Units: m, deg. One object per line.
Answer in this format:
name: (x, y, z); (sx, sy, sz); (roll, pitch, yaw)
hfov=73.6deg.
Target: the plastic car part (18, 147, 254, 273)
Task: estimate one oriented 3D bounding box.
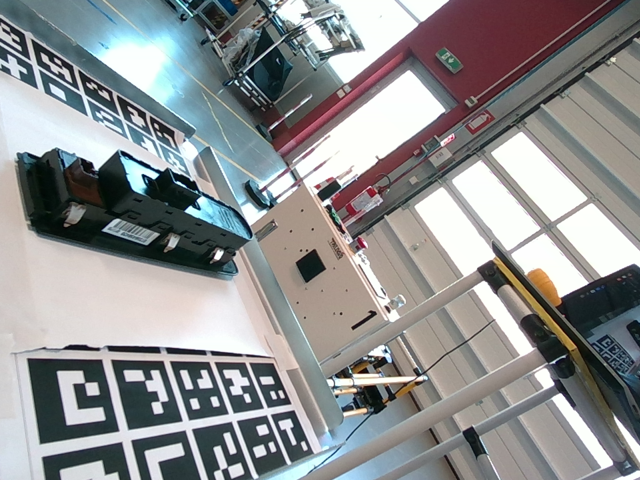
plastic car part: (-0.118, -0.022, 0.341); (0.067, 0.066, 0.202); (-41, -27, 8)
